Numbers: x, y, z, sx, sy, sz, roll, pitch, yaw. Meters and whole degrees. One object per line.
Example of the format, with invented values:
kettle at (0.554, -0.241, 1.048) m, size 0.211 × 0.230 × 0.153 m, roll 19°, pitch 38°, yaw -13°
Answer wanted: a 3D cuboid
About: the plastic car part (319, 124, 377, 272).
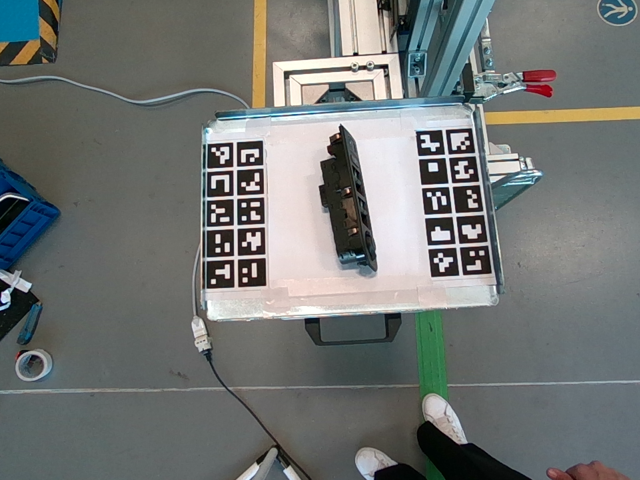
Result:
plastic car part at (0.036, -0.052, 0.592) m, size 0.067 × 0.202 × 0.066 m, roll -16°, pitch -12°, yaw 12°
